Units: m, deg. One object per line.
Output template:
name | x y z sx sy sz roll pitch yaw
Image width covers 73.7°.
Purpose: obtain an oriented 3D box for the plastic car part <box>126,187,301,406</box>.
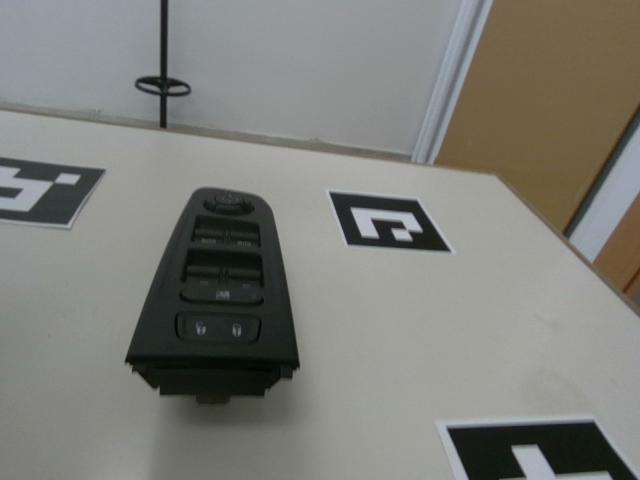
plastic car part | -0.056 0.022 0.259 0.066 0.067 0.203 0 31 -9
